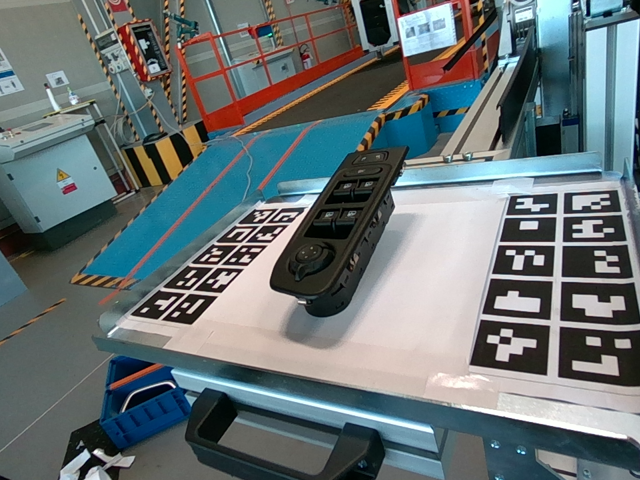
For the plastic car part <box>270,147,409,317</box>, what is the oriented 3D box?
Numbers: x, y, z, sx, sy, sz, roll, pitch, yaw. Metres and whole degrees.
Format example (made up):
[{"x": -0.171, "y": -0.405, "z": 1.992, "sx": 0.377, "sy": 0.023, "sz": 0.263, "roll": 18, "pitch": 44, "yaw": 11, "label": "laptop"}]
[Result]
[{"x": 0.023, "y": -0.010, "z": 0.371, "sx": 0.067, "sy": 0.067, "sz": 0.202, "roll": 6, "pitch": 38, "yaw": 26, "label": "plastic car part"}]
